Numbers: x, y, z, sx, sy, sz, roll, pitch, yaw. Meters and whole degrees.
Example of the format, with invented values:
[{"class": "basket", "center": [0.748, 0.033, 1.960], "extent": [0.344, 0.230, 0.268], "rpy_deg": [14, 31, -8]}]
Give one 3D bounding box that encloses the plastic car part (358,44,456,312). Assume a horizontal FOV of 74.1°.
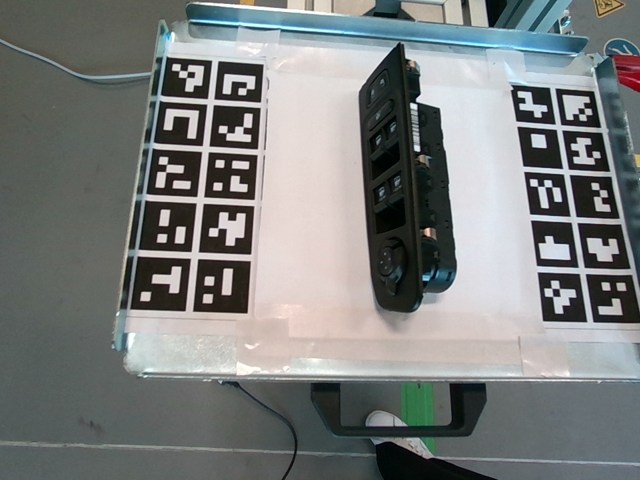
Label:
[{"class": "plastic car part", "center": [0.068, -0.042, 0.333], "extent": [0.067, 0.203, 0.067], "rpy_deg": [13, -21, -30]}]
